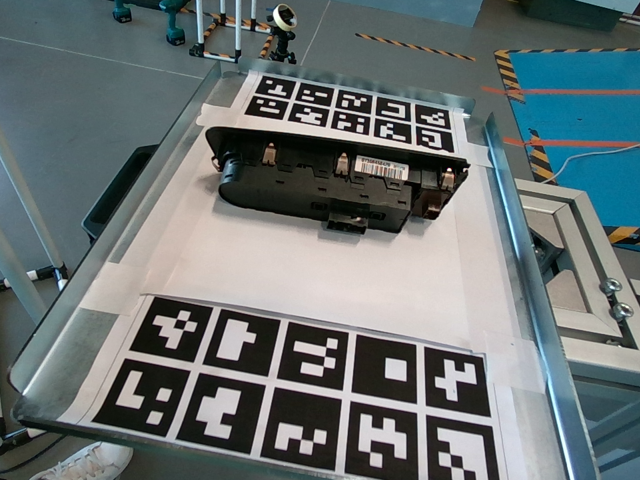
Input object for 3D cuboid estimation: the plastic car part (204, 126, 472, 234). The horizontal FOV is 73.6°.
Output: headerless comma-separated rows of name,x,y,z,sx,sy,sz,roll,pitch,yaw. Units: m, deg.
plastic car part,0.006,-0.042,0.338,0.203,0.067,0.066,13,-16,1
